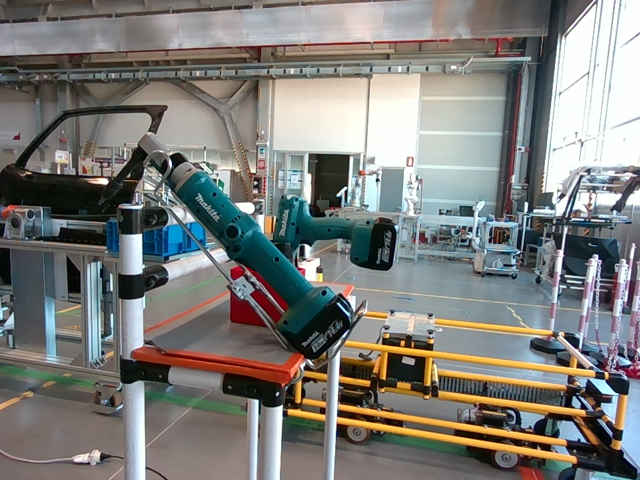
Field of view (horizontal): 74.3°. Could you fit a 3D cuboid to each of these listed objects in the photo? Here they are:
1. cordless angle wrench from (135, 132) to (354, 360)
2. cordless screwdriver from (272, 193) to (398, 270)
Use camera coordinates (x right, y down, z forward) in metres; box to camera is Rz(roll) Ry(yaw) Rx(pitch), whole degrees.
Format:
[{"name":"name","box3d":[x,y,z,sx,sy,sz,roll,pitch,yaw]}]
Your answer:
[{"name":"cordless angle wrench","box3d":[-0.123,-0.009,0.631,0.098,0.423,0.074,-45,-4,6]},{"name":"cordless screwdriver","box3d":[0.025,0.008,0.843,0.249,0.159,0.074,14,11,10]}]
